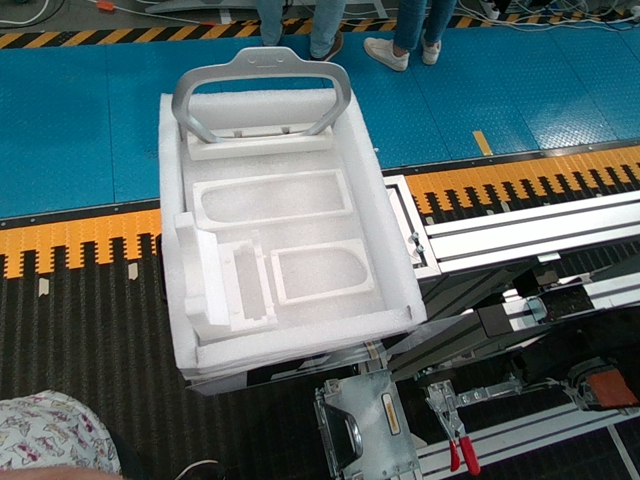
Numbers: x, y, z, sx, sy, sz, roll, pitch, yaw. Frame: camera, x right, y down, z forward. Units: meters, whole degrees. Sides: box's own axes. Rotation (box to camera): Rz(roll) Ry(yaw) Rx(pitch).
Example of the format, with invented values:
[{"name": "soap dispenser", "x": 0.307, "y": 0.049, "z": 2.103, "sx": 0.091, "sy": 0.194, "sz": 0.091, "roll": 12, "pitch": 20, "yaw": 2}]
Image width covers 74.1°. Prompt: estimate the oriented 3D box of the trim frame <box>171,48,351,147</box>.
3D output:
[{"name": "trim frame", "x": -0.076, "y": -0.187, "z": 0.586, "sx": 0.248, "sy": 0.027, "sz": 0.185, "roll": -7, "pitch": -19, "yaw": -11}]
